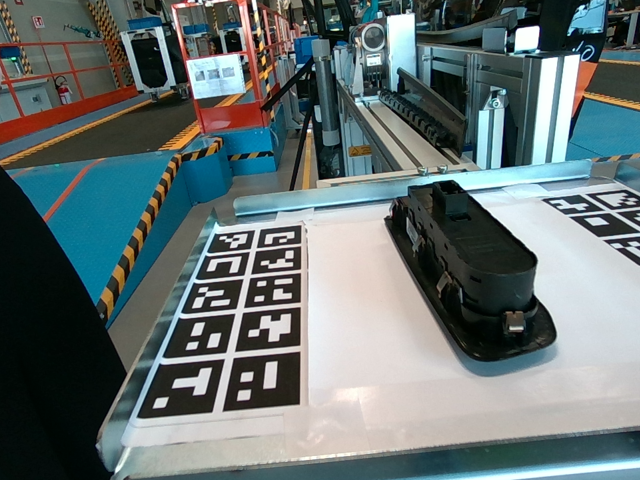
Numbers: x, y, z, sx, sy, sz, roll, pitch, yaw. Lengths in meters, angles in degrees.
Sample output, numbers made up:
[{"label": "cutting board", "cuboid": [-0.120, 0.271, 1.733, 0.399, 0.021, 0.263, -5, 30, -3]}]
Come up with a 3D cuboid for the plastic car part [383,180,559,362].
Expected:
[{"label": "plastic car part", "cuboid": [0.098, 0.000, 0.301, 0.066, 0.067, 0.202, -2, 30, -3]}]
